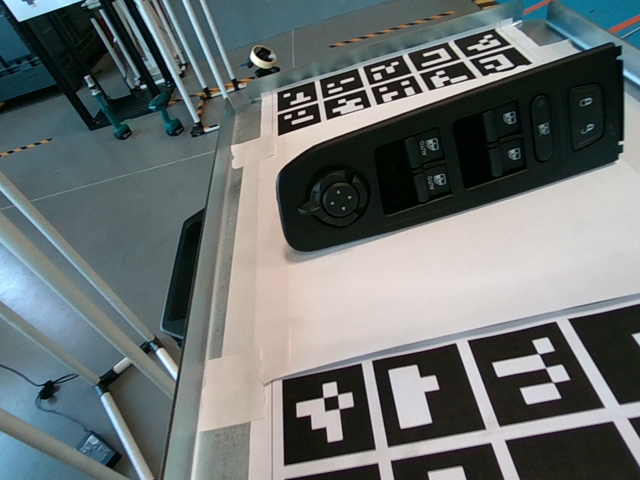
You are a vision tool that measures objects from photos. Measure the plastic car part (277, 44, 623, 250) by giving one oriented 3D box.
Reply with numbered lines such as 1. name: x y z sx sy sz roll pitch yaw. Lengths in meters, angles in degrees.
1. plastic car part: 0.068 -0.055 0.256 0.203 0.066 0.067 -20 32 -2
